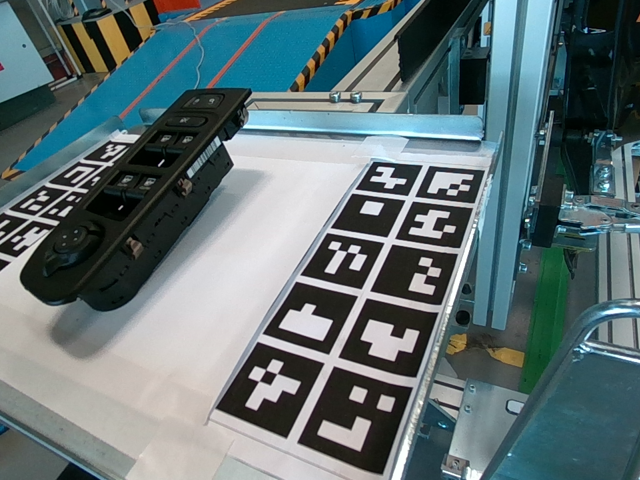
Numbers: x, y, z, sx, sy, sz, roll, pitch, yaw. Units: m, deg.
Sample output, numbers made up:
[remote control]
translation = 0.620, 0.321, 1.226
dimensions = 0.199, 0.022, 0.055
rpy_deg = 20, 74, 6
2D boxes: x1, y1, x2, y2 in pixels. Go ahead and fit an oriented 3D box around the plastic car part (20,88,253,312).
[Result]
[plastic car part]
translation = -0.116, -0.031, 0.300
dimensions = 0.066, 0.202, 0.067
rpy_deg = 15, -39, 20
